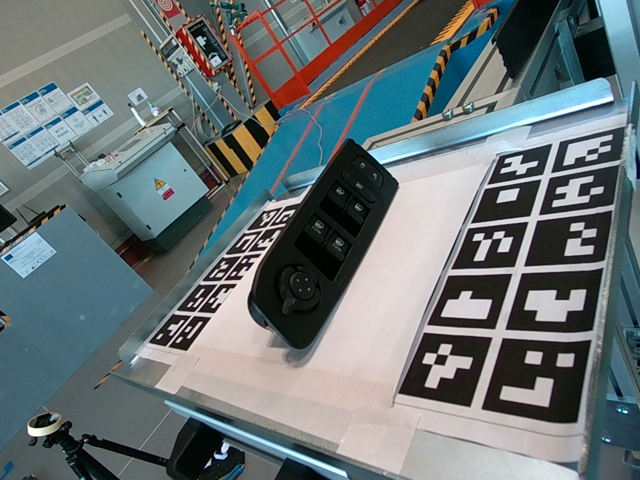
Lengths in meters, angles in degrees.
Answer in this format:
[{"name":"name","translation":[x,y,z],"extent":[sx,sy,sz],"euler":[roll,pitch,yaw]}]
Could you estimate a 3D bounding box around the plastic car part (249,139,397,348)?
[{"name":"plastic car part","translation":[-0.002,-0.002,0.354],"extent":[0.067,0.066,0.202],"euler":[-26,25,42]}]
